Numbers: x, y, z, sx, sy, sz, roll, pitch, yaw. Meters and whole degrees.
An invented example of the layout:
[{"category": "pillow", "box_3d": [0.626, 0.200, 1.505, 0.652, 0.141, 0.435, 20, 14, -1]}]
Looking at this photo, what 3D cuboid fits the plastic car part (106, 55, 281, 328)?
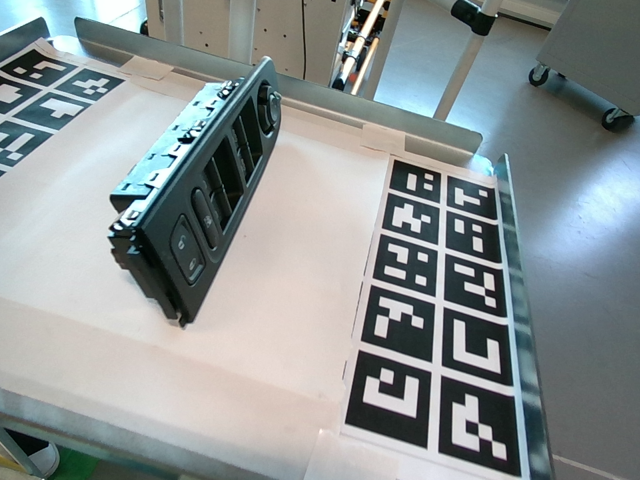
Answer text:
[{"category": "plastic car part", "box_3d": [-0.071, -0.048, 0.267, 0.068, 0.067, 0.202, 0, 45, 22]}]
